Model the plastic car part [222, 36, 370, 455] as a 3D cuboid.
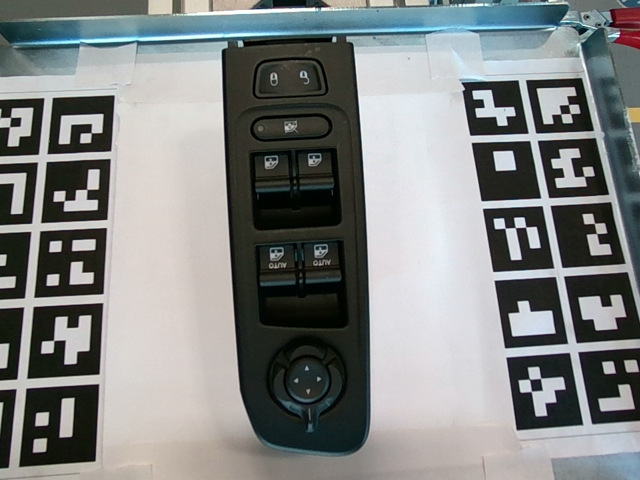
[{"bbox_3d":[-0.014,0.003,0.224,0.066,0.202,0.067,-2,-10,-10],"label":"plastic car part"}]
